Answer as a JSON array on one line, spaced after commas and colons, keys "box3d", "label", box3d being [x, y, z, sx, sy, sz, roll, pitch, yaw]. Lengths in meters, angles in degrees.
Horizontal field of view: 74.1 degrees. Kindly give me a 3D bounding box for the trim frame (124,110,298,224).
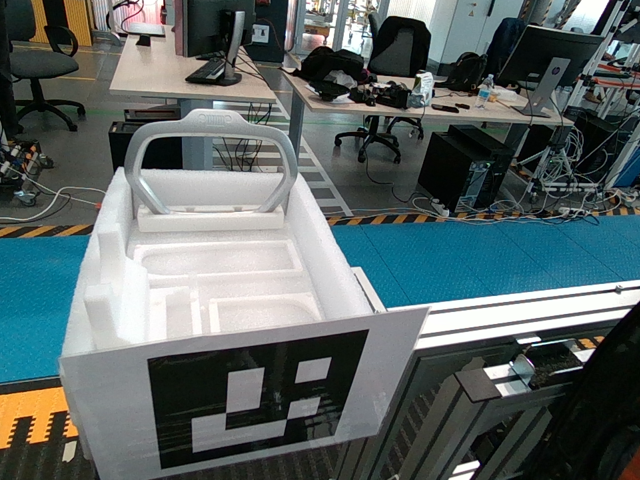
[{"box3d": [-0.153, -0.099, 0.623, 0.248, 0.185, 0.027, -2, 41, -16], "label": "trim frame"}]
